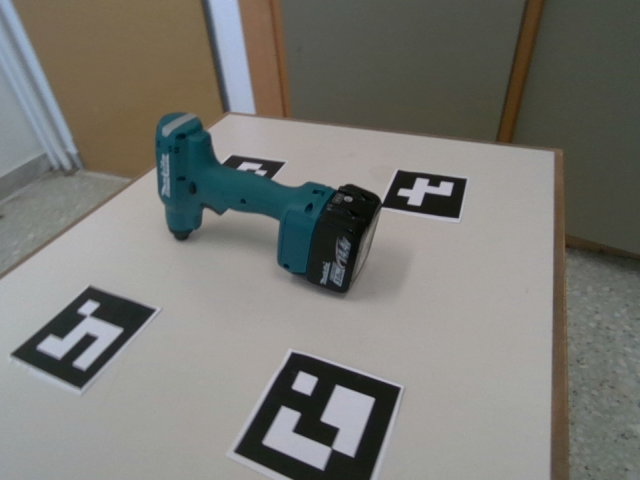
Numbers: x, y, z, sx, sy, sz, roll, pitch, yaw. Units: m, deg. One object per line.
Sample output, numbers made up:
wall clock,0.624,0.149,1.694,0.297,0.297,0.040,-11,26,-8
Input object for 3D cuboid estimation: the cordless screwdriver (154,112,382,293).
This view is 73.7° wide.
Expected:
cordless screwdriver,-0.069,-0.022,0.461,0.250,0.159,0.074,25,41,12
